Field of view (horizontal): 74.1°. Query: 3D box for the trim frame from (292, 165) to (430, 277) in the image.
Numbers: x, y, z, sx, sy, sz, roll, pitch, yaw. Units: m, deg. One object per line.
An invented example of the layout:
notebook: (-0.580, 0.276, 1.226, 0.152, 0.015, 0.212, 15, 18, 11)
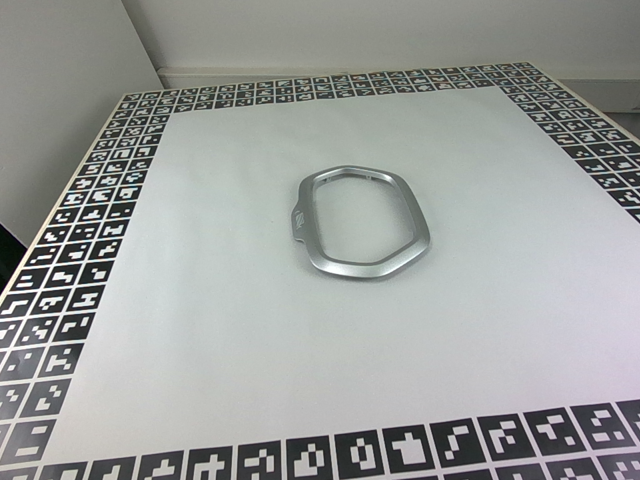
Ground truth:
trim frame: (0.051, -0.037, 0.603, 0.184, 0.027, 0.248, -7, 44, -2)
